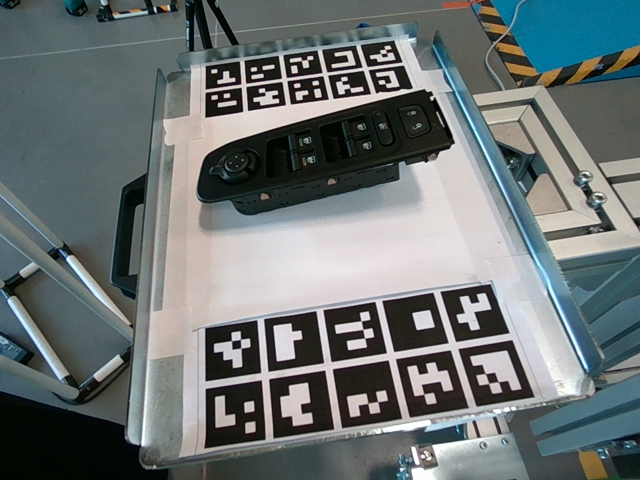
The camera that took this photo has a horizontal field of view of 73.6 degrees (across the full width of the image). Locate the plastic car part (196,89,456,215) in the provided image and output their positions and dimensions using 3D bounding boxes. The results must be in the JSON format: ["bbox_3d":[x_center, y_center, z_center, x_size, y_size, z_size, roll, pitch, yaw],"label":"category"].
[{"bbox_3d":[-0.001,-0.065,0.357,0.203,0.066,0.067,-11,-24,1],"label":"plastic car part"}]
